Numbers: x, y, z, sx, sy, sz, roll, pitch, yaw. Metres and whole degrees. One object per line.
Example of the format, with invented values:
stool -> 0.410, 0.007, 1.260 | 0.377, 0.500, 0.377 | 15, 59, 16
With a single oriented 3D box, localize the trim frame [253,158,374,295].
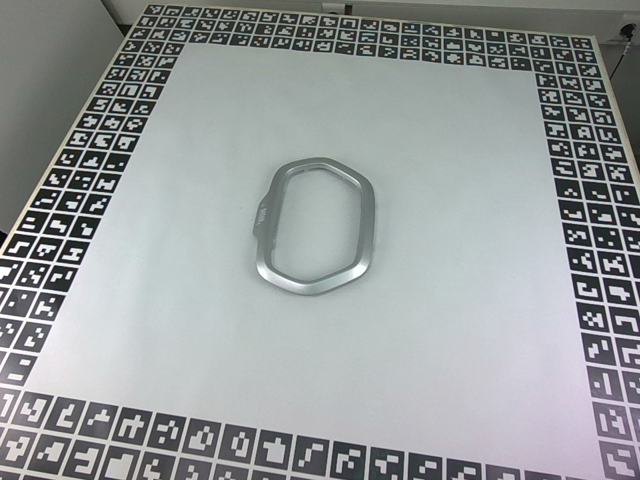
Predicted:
trim frame -> -0.010, -0.030, 0.652 | 0.184, 0.247, 0.027 | 6, -28, 3
